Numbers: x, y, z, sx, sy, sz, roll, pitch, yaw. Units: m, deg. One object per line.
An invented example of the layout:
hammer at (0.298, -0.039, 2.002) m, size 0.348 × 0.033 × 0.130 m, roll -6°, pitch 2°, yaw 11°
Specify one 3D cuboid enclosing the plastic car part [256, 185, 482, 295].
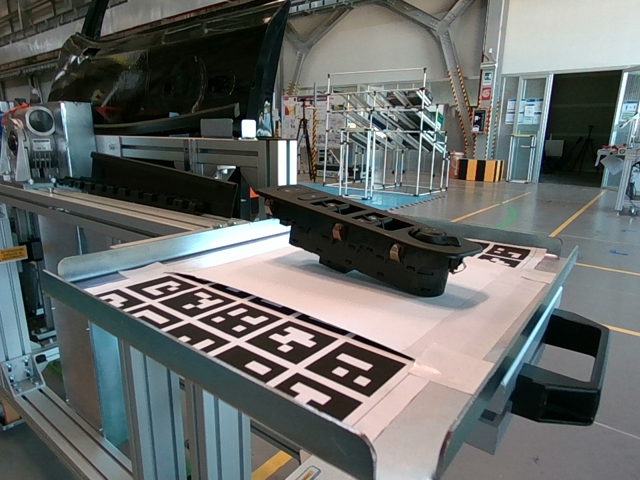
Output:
plastic car part at (0.033, -0.001, 0.378) m, size 0.204 × 0.067 × 0.066 m, roll 16°, pitch 12°, yaw 33°
